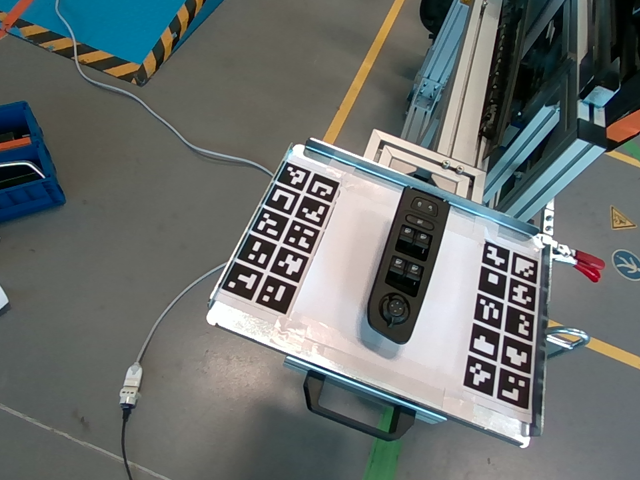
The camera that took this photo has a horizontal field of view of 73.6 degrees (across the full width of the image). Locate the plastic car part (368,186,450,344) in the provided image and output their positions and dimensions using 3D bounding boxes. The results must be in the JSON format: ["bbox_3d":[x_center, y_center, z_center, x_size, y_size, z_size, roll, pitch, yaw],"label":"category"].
[{"bbox_3d":[0.103,0.032,0.543,0.066,0.202,0.067,24,-27,-7],"label":"plastic car part"}]
